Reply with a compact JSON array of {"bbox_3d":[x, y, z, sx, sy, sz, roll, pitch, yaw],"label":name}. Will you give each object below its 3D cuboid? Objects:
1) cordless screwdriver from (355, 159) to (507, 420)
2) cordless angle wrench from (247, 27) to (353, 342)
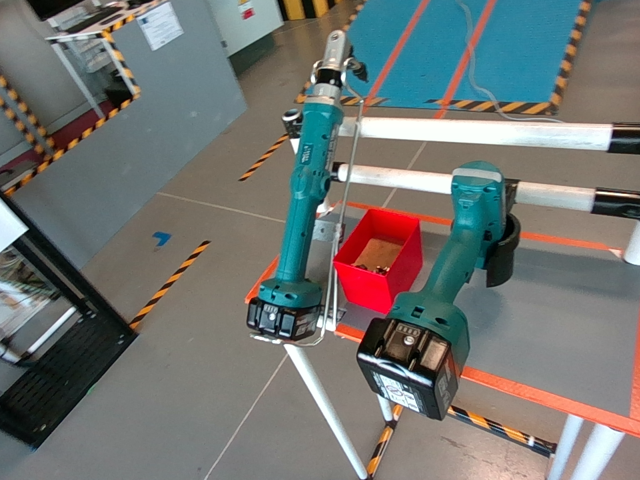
[{"bbox_3d":[0.136,0.056,0.440,0.074,0.248,0.159,14,-30,34],"label":"cordless screwdriver"},{"bbox_3d":[-0.011,-0.078,0.582,0.074,0.422,0.098,12,2,30],"label":"cordless angle wrench"}]
